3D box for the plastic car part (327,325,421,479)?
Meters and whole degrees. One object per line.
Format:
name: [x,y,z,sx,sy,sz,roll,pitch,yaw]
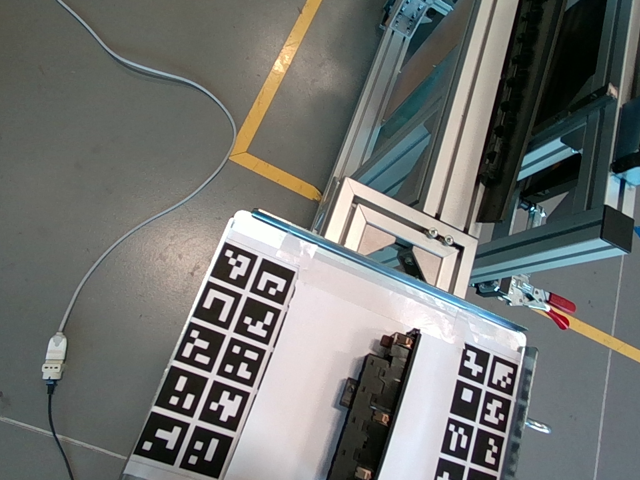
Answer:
plastic car part: [0.049,0.181,0.427,0.067,0.202,0.066,15,-14,6]
